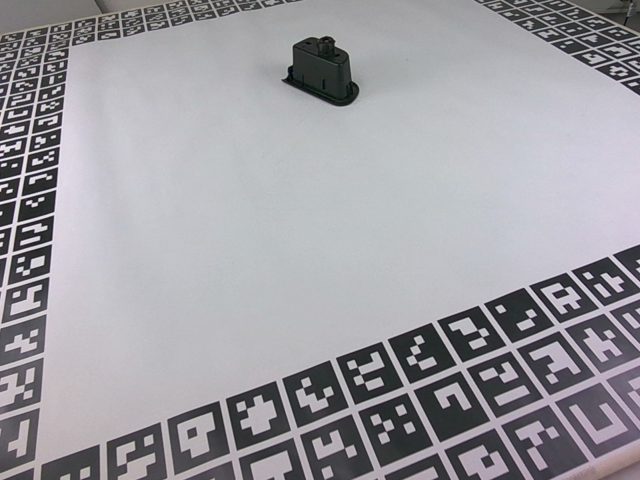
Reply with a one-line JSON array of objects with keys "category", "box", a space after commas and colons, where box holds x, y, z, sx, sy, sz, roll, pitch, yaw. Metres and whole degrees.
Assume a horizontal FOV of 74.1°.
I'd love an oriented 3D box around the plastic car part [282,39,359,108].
[{"category": "plastic car part", "box": [0.005, -0.234, 0.573, 0.066, 0.071, 0.117, -35, 51, -23]}]
